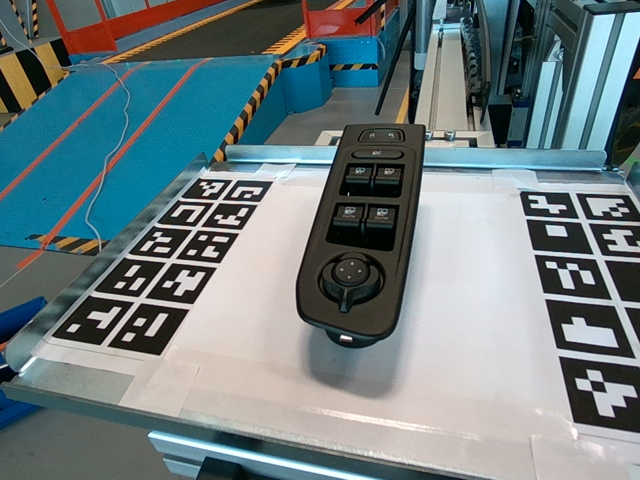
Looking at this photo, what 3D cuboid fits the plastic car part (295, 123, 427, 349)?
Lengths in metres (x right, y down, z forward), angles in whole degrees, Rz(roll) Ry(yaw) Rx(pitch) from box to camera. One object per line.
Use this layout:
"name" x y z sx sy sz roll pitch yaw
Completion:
"plastic car part" 0.031 -0.009 0.293 0.066 0.067 0.202 9 43 9
